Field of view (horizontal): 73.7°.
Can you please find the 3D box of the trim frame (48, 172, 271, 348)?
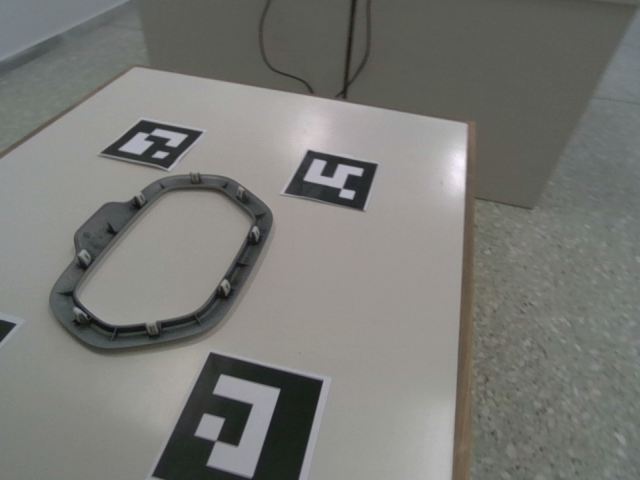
[{"bbox_3d":[-0.156,0.003,0.441,0.185,0.027,0.247,14,47,10],"label":"trim frame"}]
